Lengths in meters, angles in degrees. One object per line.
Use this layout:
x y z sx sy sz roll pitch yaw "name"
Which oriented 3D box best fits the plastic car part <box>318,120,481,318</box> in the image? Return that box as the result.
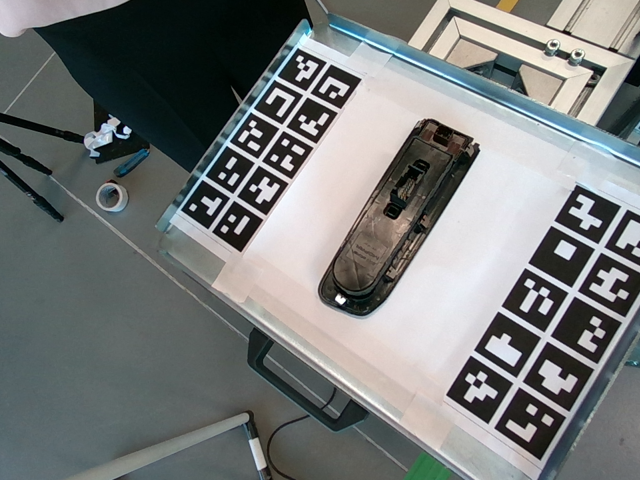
0.069 -0.021 0.378 0.066 0.203 0.067 32 -3 10 "plastic car part"
